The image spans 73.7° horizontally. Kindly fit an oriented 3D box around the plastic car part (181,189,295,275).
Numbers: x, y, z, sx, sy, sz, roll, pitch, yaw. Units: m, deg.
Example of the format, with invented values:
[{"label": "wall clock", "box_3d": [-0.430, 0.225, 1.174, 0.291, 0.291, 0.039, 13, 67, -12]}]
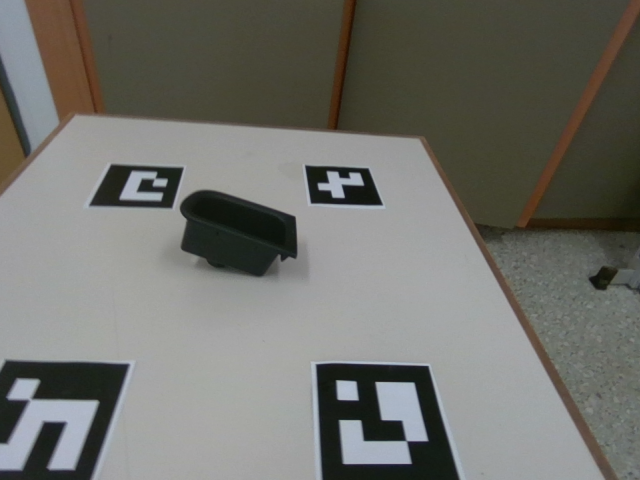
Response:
[{"label": "plastic car part", "box_3d": [-0.091, -0.001, 0.444, 0.116, 0.071, 0.066, 18, 39, -18]}]
